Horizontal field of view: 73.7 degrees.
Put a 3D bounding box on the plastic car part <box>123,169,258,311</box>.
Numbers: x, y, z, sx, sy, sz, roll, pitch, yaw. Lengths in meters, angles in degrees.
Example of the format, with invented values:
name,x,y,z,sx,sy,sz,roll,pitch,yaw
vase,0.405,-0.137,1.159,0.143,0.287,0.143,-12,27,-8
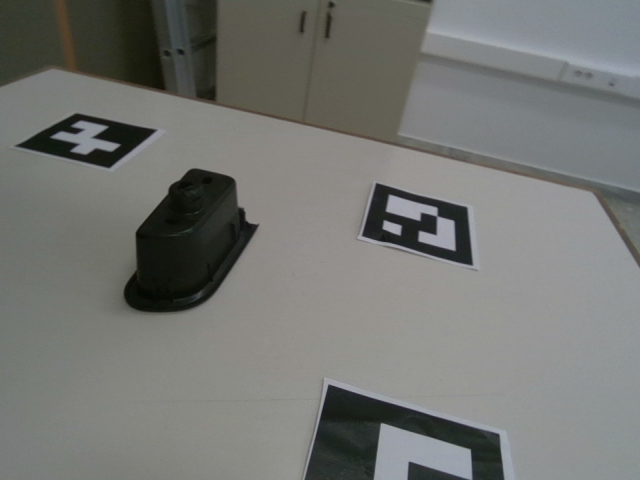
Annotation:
name,x,y,z,sx,sy,sz,roll,pitch,yaw
plastic car part,-0.091,-0.011,0.305,0.066,0.071,0.116,14,34,5
